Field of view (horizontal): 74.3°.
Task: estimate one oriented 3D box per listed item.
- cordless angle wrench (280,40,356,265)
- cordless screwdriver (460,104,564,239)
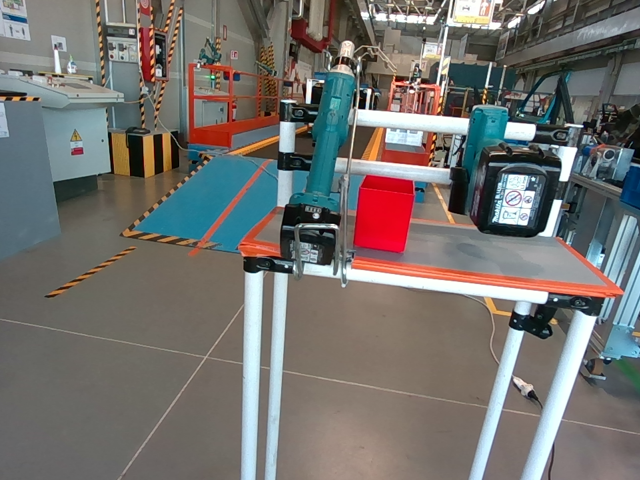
[{"bbox_3d":[0.016,-0.168,0.660,0.074,0.421,0.098,11,-28,0],"label":"cordless angle wrench"},{"bbox_3d":[0.221,-0.074,0.547,0.074,0.159,0.248,7,28,8],"label":"cordless screwdriver"}]
